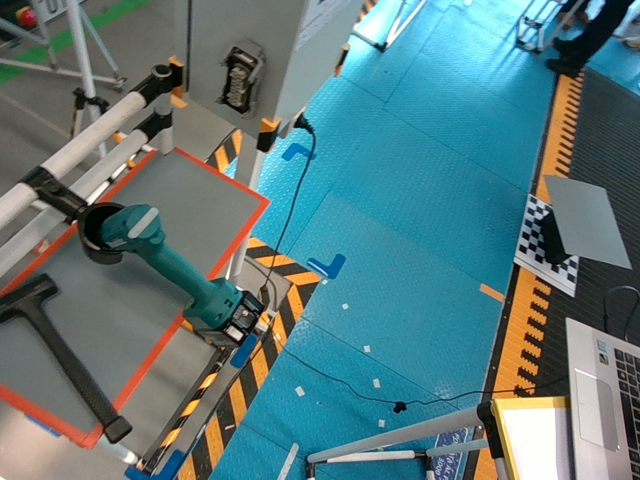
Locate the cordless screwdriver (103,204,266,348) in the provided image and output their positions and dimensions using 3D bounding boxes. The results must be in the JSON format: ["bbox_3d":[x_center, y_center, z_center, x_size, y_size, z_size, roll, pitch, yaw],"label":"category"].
[{"bbox_3d":[-0.207,0.056,0.616,0.159,0.074,0.249,-11,-52,48],"label":"cordless screwdriver"}]
